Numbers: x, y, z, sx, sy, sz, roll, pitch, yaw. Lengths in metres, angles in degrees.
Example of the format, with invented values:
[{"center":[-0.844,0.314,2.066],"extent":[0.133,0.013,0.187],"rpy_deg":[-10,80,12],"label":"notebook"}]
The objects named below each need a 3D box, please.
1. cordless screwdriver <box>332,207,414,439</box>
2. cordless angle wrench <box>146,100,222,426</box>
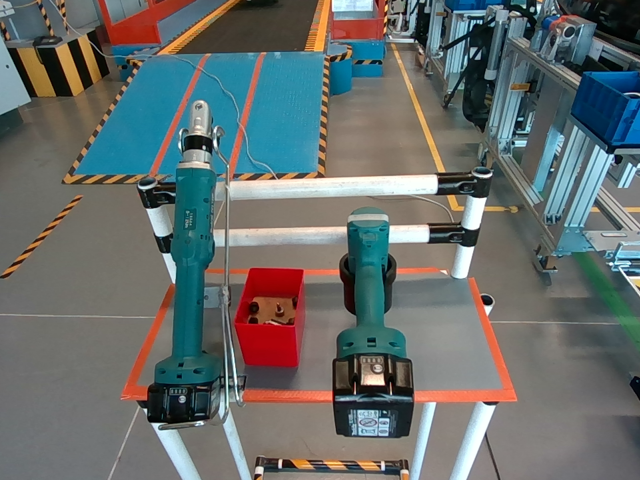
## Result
[{"center":[0.058,0.099,0.492],"extent":[0.074,0.248,0.159],"rpy_deg":[-1,-44,6],"label":"cordless screwdriver"},{"center":[-0.166,0.013,0.557],"extent":[0.074,0.422,0.098],"rpy_deg":[0,-10,-3],"label":"cordless angle wrench"}]
